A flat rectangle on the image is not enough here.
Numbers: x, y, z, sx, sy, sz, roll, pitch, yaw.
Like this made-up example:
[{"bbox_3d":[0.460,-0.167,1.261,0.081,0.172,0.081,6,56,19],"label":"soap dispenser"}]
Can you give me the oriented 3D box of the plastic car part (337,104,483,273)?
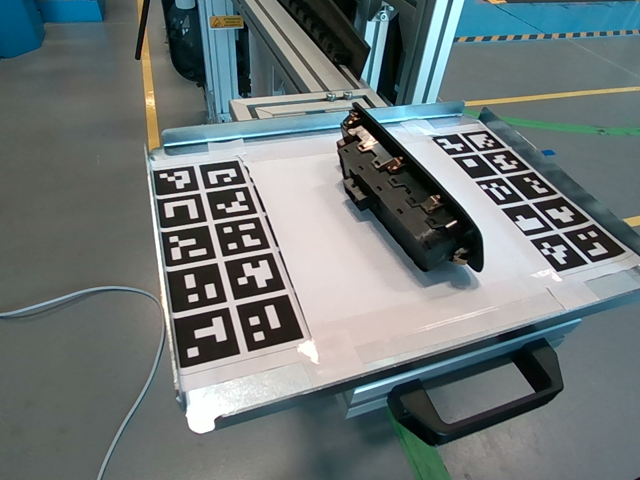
[{"bbox_3d":[0.067,-0.045,0.387,0.067,0.203,0.066,-27,-37,-15],"label":"plastic car part"}]
